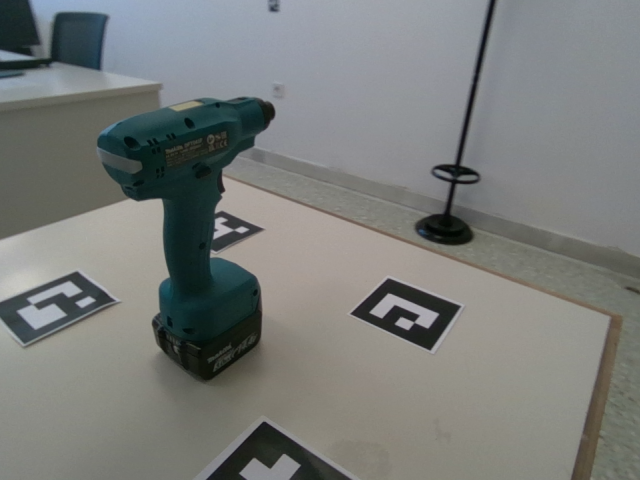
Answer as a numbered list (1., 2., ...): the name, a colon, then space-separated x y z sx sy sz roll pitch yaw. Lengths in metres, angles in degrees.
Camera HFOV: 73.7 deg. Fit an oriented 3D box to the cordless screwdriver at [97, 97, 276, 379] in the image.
1. cordless screwdriver: -0.097 -0.004 0.401 0.075 0.249 0.158 23 38 31
